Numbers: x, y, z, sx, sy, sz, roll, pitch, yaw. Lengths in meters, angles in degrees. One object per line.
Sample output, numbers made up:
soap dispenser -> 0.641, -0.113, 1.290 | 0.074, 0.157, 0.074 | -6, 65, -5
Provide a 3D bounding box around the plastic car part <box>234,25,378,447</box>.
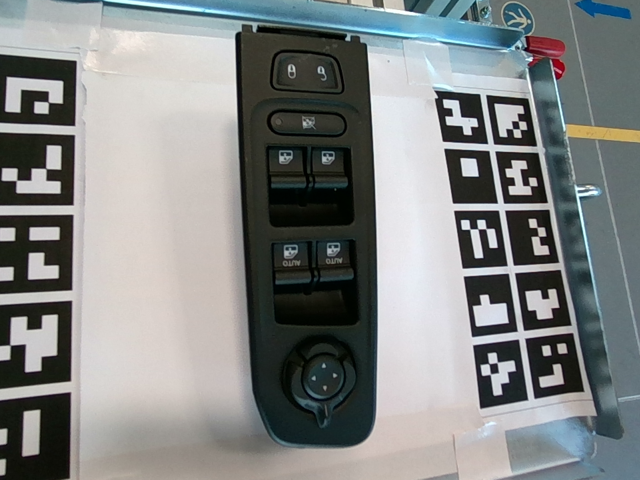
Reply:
plastic car part -> -0.011, 0.002, 0.220 | 0.066, 0.202, 0.067 | -2, -5, -24
